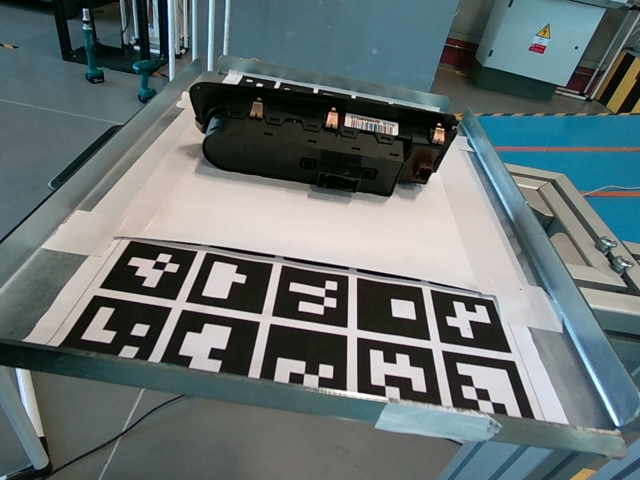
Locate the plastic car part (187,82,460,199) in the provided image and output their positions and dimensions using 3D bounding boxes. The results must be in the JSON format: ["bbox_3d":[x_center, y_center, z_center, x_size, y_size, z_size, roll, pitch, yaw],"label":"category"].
[{"bbox_3d":[-0.003,-0.069,0.327,0.203,0.067,0.067,12,-26,-2],"label":"plastic car part"}]
